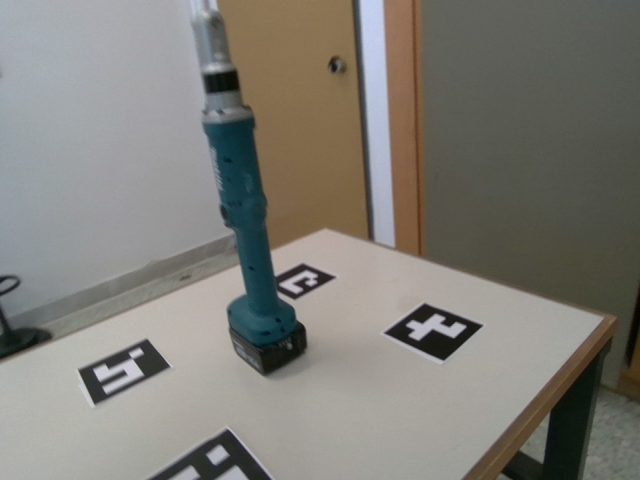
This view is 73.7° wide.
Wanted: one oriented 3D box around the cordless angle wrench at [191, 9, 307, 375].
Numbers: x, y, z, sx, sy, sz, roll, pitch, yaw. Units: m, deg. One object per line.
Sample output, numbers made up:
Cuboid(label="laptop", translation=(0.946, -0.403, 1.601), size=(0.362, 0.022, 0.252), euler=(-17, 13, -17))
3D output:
Cuboid(label="cordless angle wrench", translation=(-0.092, -0.039, 0.512), size=(0.073, 0.422, 0.099), euler=(-23, 26, -35))
